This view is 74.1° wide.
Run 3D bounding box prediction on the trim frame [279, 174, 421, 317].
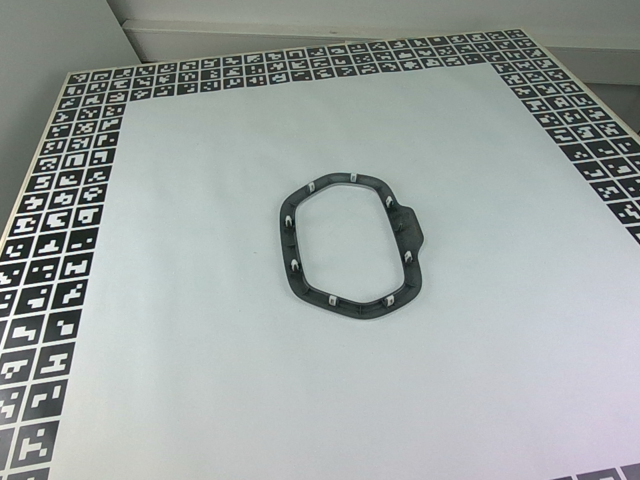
[{"bbox_3d":[0.038,-0.007,0.570,0.184,0.248,0.027,-7,-41,-2],"label":"trim frame"}]
